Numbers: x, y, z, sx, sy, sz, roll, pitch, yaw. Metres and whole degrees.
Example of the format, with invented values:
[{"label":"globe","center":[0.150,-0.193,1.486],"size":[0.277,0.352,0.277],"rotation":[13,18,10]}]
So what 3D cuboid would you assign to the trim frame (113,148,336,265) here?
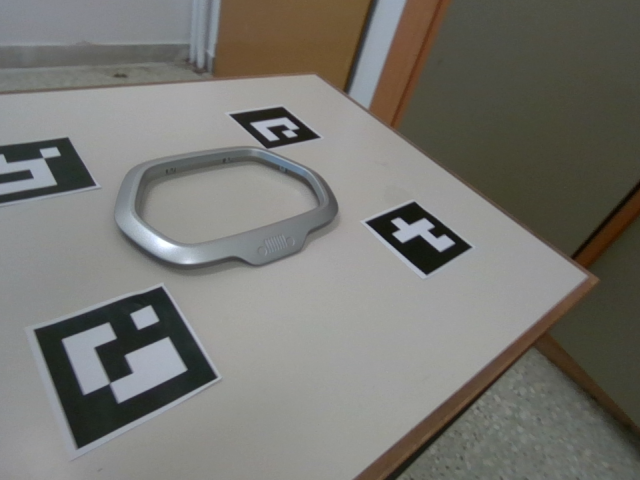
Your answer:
[{"label":"trim frame","center":[-0.096,-0.045,0.471],"size":[0.246,0.027,0.185],"rotation":[-19,51,-38]}]
